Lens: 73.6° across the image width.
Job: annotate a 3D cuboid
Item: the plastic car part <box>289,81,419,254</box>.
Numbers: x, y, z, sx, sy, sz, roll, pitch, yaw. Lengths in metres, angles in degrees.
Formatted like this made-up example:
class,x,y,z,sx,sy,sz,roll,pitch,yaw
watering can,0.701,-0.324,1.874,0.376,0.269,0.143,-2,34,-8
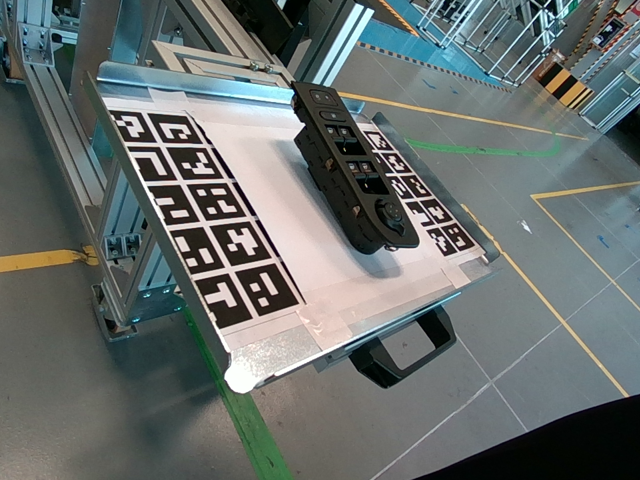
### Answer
class,x,y,z,sx,sy,sz,roll,pitch,yaw
plastic car part,0.024,-0.067,0.435,0.067,0.203,0.066,-43,-22,31
